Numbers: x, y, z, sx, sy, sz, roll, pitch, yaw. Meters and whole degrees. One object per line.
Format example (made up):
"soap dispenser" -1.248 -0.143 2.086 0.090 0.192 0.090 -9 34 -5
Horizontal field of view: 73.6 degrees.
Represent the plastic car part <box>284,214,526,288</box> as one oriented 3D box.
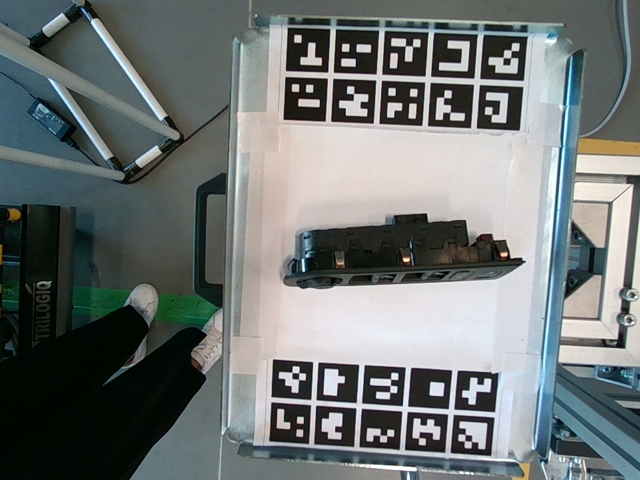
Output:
"plastic car part" 0.065 0.012 0.381 0.203 0.067 0.066 -7 -8 3
